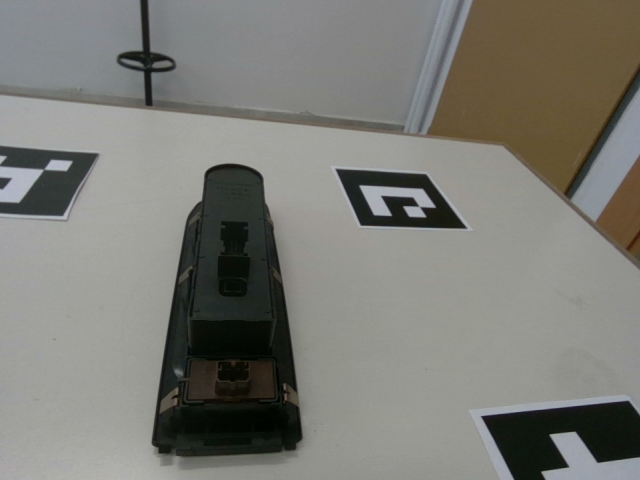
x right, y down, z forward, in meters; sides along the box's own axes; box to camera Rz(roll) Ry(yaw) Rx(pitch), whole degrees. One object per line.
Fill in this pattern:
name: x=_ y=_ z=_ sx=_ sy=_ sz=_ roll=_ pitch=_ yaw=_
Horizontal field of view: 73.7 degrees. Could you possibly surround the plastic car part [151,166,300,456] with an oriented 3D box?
plastic car part: x=-0.056 y=0.015 z=0.255 sx=0.066 sy=0.067 sz=0.203 roll=-3 pitch=35 yaw=-9
